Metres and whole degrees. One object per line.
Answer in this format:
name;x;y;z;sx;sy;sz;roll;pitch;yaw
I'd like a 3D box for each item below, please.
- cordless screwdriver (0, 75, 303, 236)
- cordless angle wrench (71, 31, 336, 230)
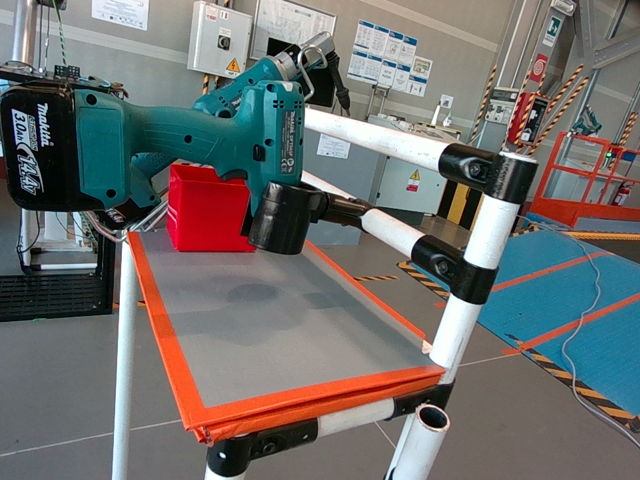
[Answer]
cordless screwdriver;-0.131;-0.065;0.383;0.248;0.159;0.074;-9;25;-28
cordless angle wrench;-0.145;-0.179;0.606;0.422;0.098;0.074;-39;40;-10
